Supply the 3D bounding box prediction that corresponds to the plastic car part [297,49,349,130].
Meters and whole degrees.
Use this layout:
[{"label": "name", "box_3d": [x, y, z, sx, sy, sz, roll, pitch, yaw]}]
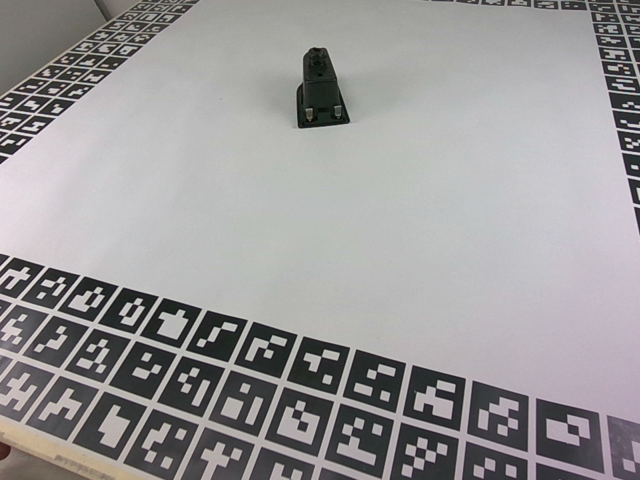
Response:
[{"label": "plastic car part", "box_3d": [-0.002, -0.207, 0.554, 0.066, 0.116, 0.071, -6, -37, -1]}]
